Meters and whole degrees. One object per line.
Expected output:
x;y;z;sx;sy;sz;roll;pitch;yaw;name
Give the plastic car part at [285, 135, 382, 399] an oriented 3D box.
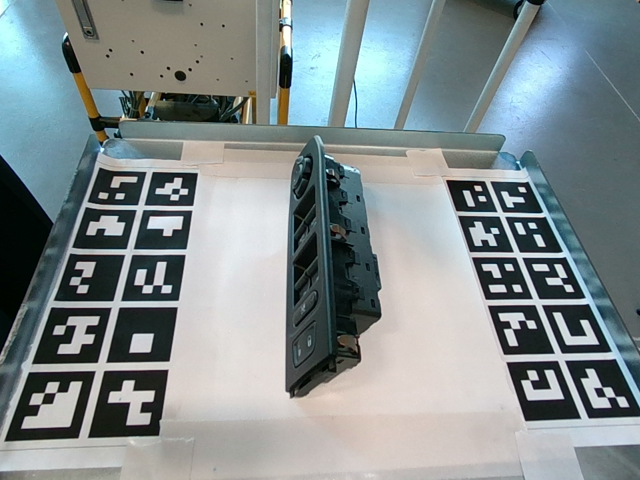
0.009;0.003;0.308;0.067;0.202;0.066;6;-38;-18;plastic car part
